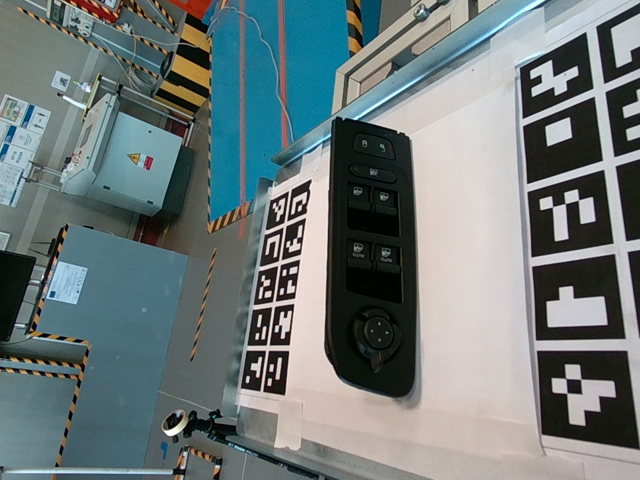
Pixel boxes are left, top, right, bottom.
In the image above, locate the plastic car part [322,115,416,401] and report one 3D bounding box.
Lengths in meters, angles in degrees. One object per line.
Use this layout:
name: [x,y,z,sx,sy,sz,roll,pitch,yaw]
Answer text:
plastic car part: [0.027,0.009,0.309,0.066,0.202,0.067,14,-30,-23]
